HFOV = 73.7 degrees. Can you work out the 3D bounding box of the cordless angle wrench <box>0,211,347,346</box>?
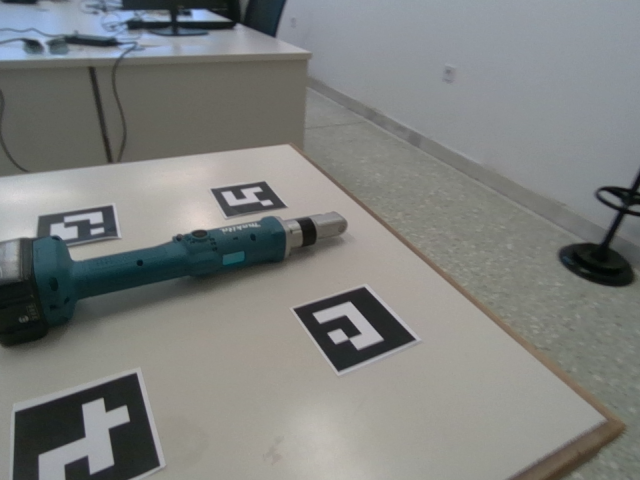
[{"bbox_3d":[-0.148,0.015,0.519,0.419,0.074,0.099,-13,35,-26],"label":"cordless angle wrench"}]
